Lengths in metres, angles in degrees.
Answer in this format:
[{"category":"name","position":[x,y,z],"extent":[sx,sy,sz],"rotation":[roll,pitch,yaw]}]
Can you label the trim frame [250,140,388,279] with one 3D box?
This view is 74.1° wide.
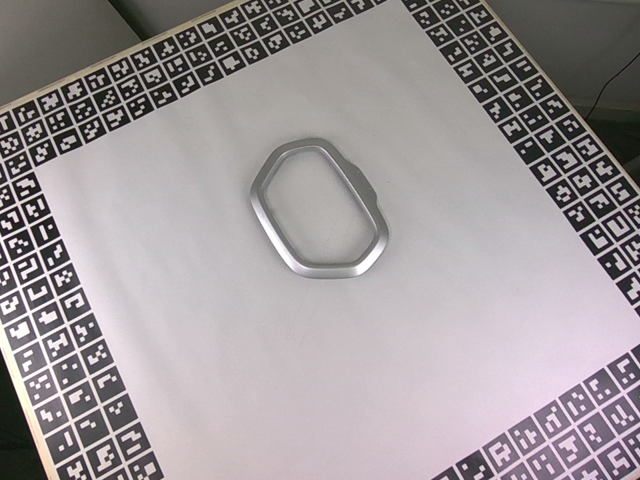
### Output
[{"category":"trim frame","position":[-0.002,-0.051,0.671],"extent":[0.184,0.248,0.027],"rotation":[-32,-17,-4]}]
